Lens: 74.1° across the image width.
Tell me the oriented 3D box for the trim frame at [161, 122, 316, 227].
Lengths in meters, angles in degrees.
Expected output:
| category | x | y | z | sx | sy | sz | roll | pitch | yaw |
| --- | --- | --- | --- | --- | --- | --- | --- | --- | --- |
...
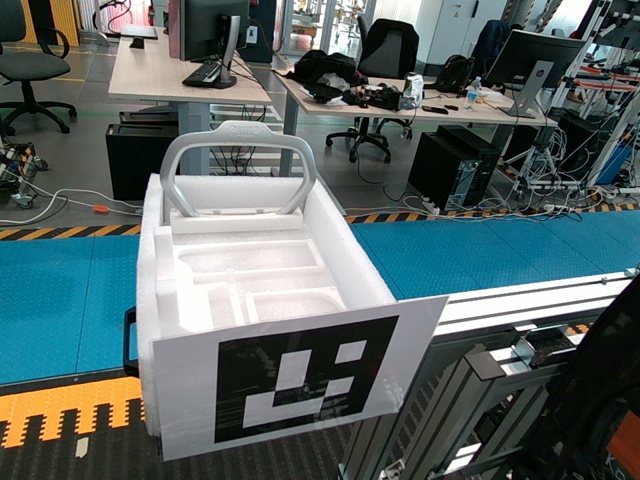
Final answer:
| category | x | y | z | sx | sy | sz | roll | pitch | yaw |
| --- | --- | --- | --- | --- | --- | --- | --- | --- | --- |
| trim frame | -0.125 | -0.099 | 0.682 | 0.248 | 0.184 | 0.027 | -4 | 39 | -18 |
